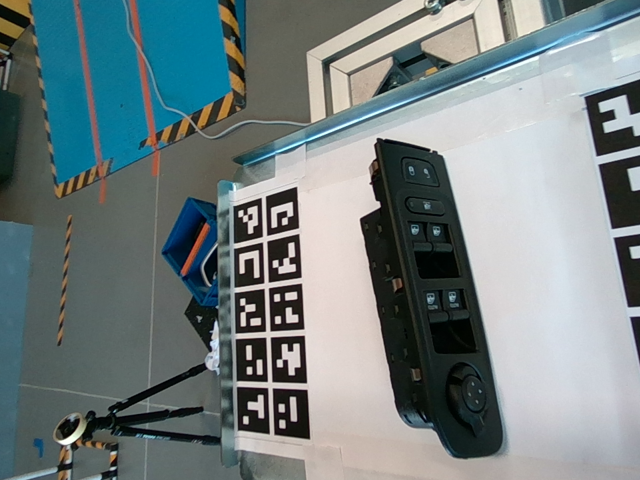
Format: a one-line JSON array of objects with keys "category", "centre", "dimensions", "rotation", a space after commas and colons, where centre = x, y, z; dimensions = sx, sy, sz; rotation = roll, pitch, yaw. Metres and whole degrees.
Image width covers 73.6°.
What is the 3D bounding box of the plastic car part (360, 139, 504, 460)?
[{"category": "plastic car part", "centre": [0.064, 0.037, 0.283], "dimensions": [0.066, 0.202, 0.067], "rotation": [5, -25, -41]}]
